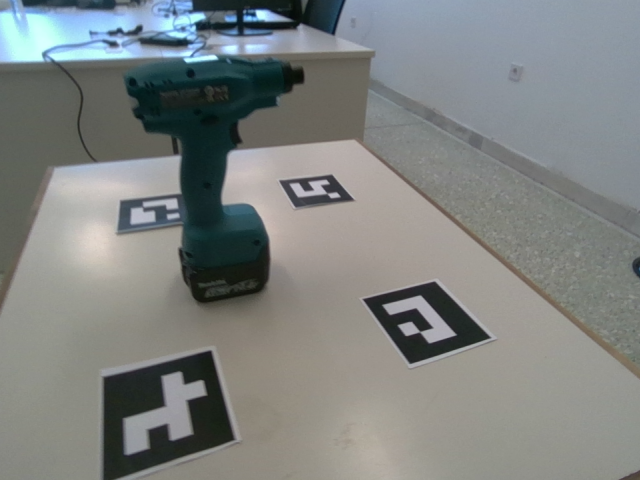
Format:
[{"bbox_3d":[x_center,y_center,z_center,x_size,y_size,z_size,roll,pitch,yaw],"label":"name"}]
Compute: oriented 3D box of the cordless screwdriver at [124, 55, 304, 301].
[{"bbox_3d":[-0.089,-0.060,0.446,0.158,0.248,0.075,-12,35,-14],"label":"cordless screwdriver"}]
